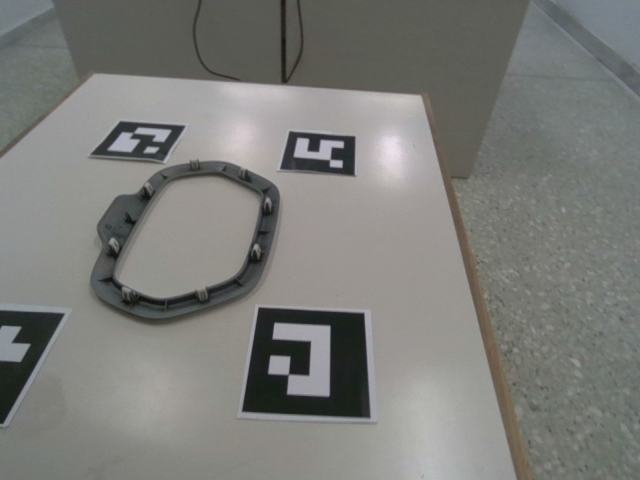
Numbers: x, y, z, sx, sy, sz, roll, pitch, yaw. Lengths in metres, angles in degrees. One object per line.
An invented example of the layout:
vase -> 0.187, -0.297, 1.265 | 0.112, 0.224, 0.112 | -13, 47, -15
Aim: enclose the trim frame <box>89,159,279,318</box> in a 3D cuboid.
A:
trim frame -> -0.141, -0.018, 0.464 | 0.184, 0.027, 0.248 | 5, 45, 3
